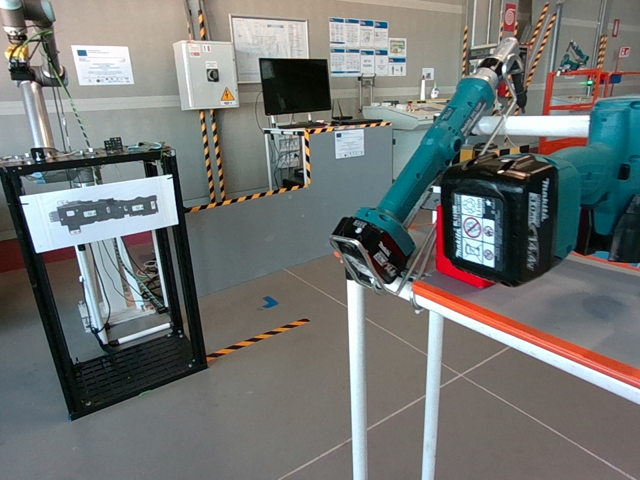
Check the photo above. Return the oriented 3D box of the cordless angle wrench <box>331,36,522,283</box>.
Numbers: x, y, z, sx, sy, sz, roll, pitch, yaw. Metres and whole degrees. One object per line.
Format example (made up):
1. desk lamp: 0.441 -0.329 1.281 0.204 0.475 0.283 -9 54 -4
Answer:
1. cordless angle wrench: 0.176 -0.136 0.611 0.074 0.422 0.098 26 -14 47

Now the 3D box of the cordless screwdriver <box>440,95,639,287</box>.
1. cordless screwdriver: 0.219 -0.028 0.382 0.248 0.159 0.074 -23 25 -28
